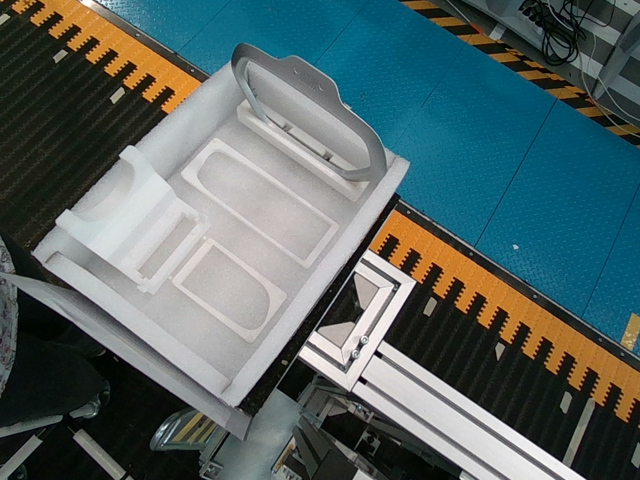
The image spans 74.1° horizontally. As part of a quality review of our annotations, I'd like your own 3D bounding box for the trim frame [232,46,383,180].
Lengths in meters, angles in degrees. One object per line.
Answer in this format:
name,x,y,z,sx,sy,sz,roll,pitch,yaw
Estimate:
trim frame,-0.019,-0.162,0.564,0.249,0.027,0.184,37,-14,7
